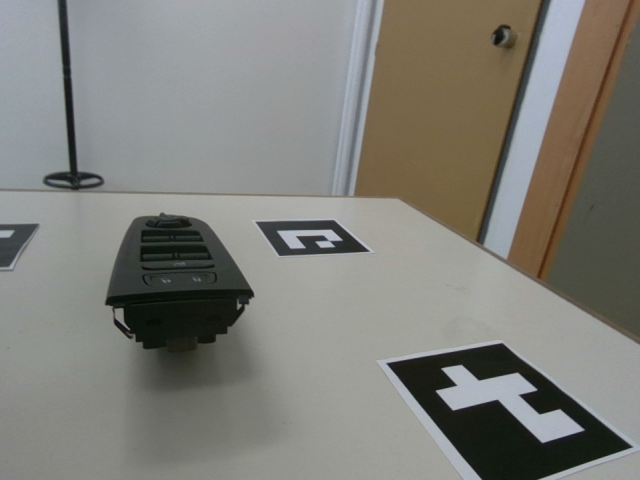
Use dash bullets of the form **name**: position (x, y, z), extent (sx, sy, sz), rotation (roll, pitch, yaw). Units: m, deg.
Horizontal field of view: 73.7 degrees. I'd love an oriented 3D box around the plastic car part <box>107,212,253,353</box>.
- **plastic car part**: position (-0.097, 0.023, 0.295), extent (0.066, 0.067, 0.204), rotation (-9, 22, -18)
